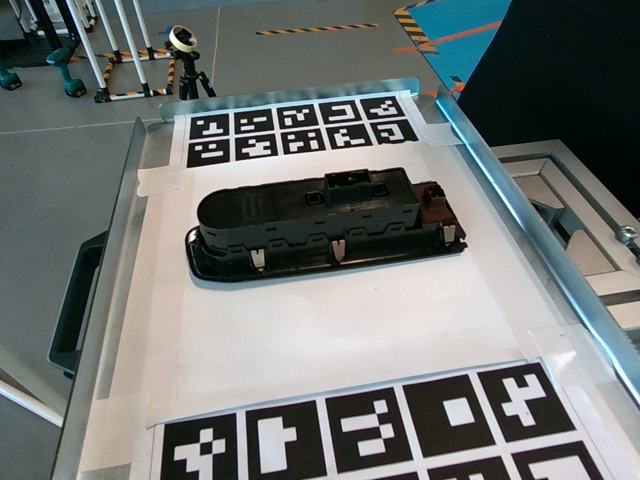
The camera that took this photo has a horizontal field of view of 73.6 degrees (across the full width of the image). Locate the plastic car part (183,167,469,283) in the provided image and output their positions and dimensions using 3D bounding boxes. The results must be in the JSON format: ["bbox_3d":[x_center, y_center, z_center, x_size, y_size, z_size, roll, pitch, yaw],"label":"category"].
[{"bbox_3d":[0.002,-0.013,0.299,0.203,0.066,0.067,-10,-36,-3],"label":"plastic car part"}]
